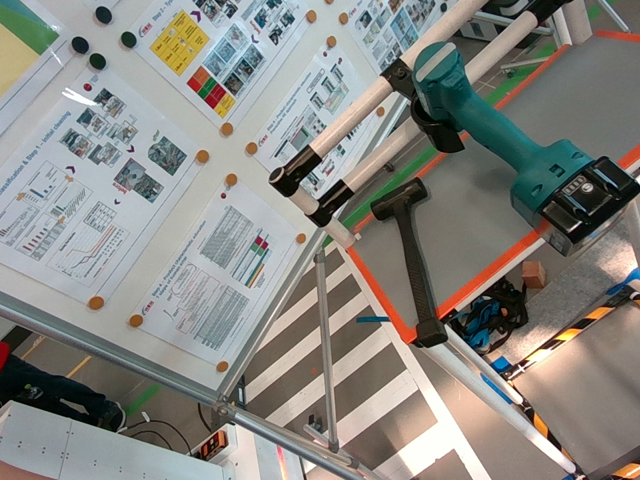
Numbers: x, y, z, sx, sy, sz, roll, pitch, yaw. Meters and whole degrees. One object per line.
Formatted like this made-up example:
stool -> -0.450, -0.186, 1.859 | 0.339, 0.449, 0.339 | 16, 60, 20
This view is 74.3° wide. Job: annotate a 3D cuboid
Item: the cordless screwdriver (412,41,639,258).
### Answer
cordless screwdriver -> 0.203, -0.096, 0.460 | 0.074, 0.248, 0.159 | -42, -22, 11
